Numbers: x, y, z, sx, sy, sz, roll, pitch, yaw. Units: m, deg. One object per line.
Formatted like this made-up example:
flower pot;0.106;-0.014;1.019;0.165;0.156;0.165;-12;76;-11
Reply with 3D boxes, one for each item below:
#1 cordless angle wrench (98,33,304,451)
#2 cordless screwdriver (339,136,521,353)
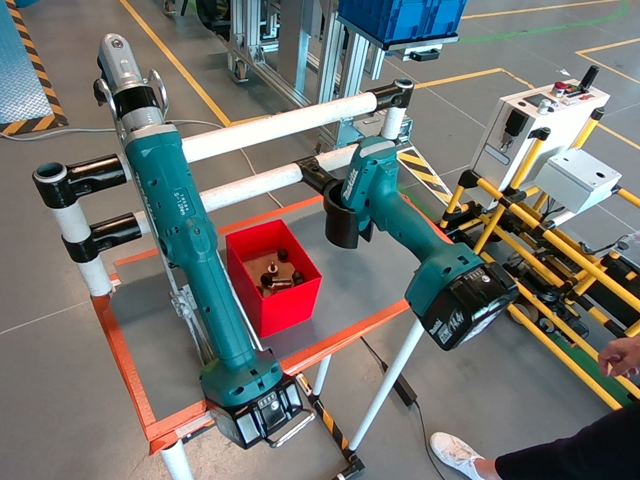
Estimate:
cordless angle wrench;-0.133;0.000;0.431;0.074;0.423;0.098;-23;6;-32
cordless screwdriver;0.103;0.013;0.508;0.074;0.248;0.160;-21;-28;-25
